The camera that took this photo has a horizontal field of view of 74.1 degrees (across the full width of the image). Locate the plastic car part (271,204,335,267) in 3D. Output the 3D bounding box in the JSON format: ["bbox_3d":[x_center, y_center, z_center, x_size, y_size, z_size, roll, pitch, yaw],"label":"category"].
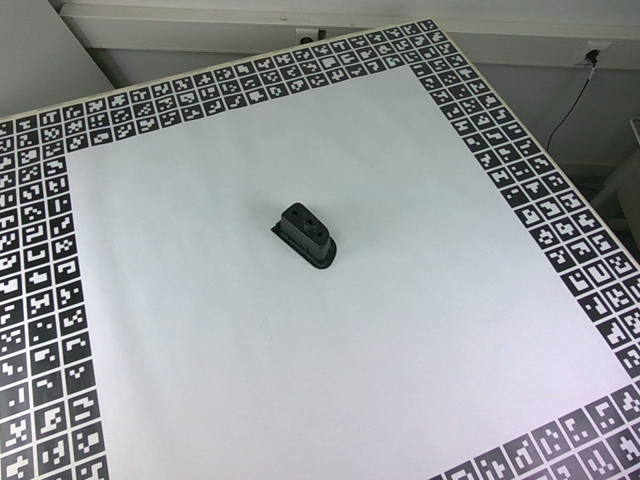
[{"bbox_3d":[-0.021,-0.017,0.700,0.117,0.066,0.071,40,-20,22],"label":"plastic car part"}]
